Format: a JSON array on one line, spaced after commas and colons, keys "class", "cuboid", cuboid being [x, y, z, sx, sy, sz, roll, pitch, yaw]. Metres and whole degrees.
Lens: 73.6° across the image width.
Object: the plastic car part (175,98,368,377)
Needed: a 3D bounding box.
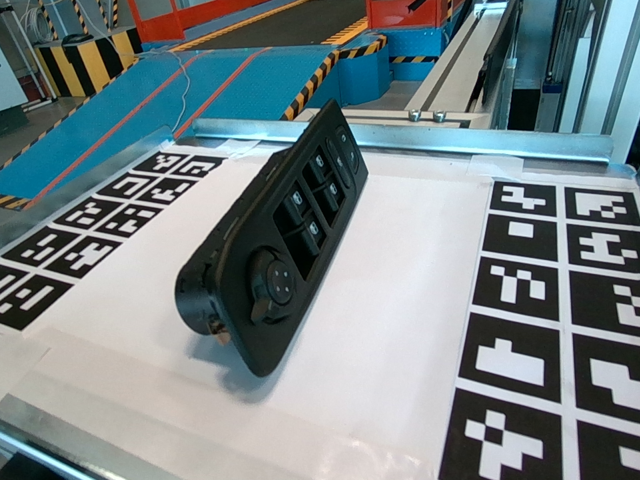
[{"class": "plastic car part", "cuboid": [-0.024, -0.016, 0.254, 0.067, 0.066, 0.202, -8, 34, 21]}]
